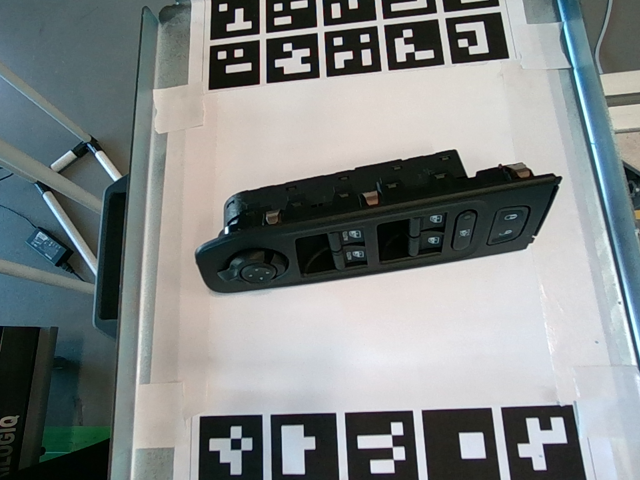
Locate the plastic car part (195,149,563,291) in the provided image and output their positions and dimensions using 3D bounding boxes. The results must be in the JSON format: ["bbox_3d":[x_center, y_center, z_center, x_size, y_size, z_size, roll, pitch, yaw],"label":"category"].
[{"bbox_3d":[0.023,-0.015,0.254,0.203,0.067,0.066,-14,-27,2],"label":"plastic car part"}]
